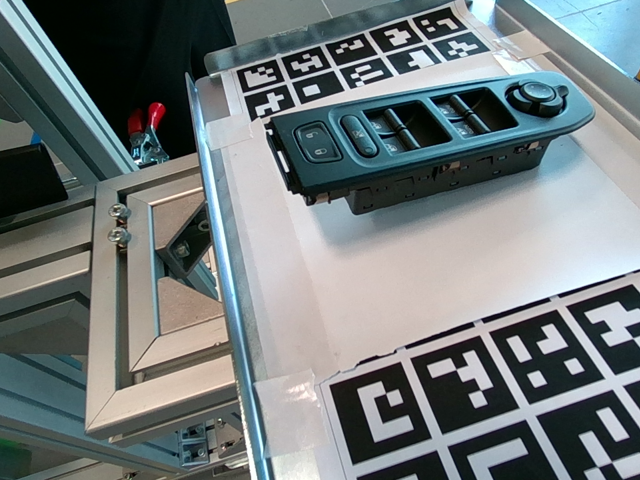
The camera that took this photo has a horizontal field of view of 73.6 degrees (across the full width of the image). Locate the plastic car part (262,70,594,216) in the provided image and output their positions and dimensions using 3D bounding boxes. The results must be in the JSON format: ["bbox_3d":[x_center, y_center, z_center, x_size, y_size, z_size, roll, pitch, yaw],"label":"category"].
[{"bbox_3d":[0.073,-0.057,0.267,0.203,0.067,0.066,-18,47,-7],"label":"plastic car part"}]
